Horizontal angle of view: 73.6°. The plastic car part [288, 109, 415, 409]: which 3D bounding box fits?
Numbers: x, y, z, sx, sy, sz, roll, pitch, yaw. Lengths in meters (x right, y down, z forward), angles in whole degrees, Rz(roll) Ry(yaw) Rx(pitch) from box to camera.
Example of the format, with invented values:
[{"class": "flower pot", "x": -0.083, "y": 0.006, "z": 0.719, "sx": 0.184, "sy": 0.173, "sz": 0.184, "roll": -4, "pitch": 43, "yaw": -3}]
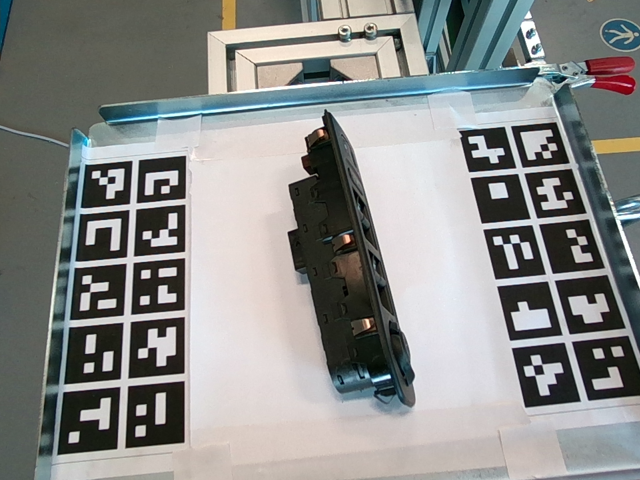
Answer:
[{"class": "plastic car part", "x": 0.016, "y": 0.015, "z": 0.293, "sx": 0.067, "sy": 0.203, "sz": 0.066, "roll": -19, "pitch": -20, "yaw": 7}]
